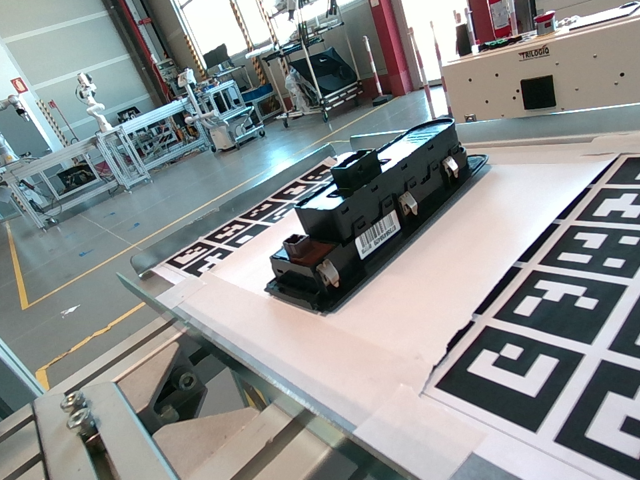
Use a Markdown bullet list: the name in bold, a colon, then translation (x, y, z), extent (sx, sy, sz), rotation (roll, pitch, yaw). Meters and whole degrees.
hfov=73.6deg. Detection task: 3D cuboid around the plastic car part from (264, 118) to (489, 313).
- **plastic car part**: translation (0.044, -0.034, 0.301), extent (0.202, 0.067, 0.067), rotation (-33, 18, -32)
